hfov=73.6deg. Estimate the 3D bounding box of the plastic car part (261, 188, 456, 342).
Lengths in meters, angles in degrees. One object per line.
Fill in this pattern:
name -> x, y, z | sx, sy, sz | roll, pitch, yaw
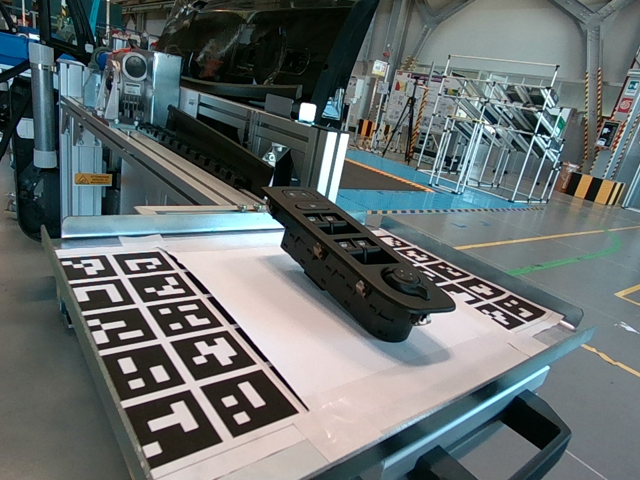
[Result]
plastic car part -> 0.019, 0.017, 0.369 | 0.066, 0.067, 0.204 | 5, 23, -44
